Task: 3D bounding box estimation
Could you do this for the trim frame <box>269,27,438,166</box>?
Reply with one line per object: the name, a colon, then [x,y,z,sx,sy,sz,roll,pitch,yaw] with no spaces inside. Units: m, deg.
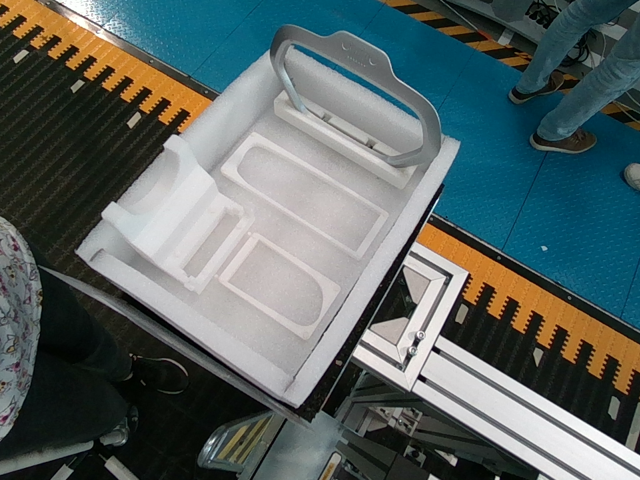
trim frame: [0.039,-0.176,0.540,0.249,0.027,0.184,33,-16,10]
